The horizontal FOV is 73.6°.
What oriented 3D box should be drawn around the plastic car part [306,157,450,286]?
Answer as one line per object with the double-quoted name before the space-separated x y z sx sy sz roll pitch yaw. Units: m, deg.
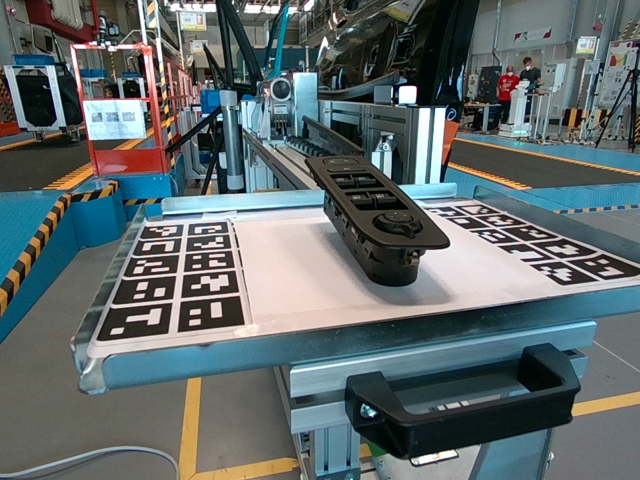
"plastic car part" 0.039 -0.022 0.380 0.066 0.067 0.203 2 23 -17
